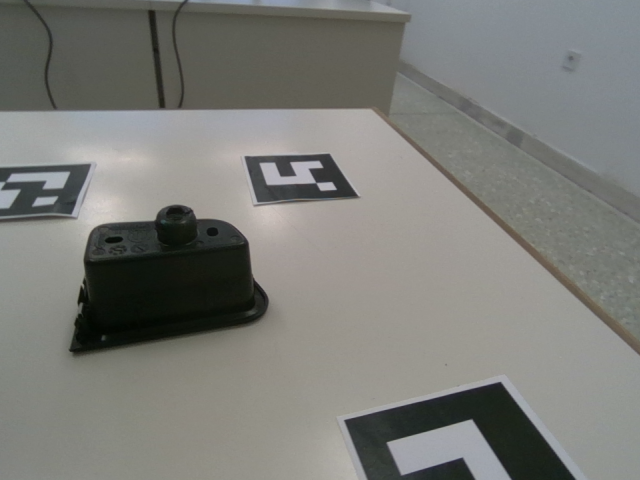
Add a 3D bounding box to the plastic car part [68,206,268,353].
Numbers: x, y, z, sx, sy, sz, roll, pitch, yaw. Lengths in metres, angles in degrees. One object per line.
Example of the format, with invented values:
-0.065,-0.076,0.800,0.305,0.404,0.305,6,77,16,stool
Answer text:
-0.092,0.015,0.261,0.116,0.071,0.066,-9,38,-14,plastic car part
